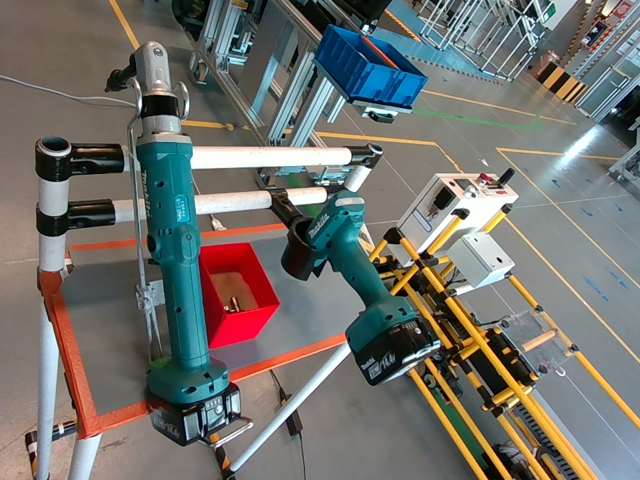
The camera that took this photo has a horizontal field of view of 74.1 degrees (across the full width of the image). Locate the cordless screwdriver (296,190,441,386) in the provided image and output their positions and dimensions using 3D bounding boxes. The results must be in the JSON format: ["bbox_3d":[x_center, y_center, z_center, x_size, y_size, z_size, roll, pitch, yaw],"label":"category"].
[{"bbox_3d":[0.046,0.072,0.585,0.074,0.248,0.159,-7,-29,-37],"label":"cordless screwdriver"}]

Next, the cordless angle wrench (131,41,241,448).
[{"bbox_3d":[-0.162,0.002,0.464,0.098,0.422,0.074,-2,6,42],"label":"cordless angle wrench"}]
